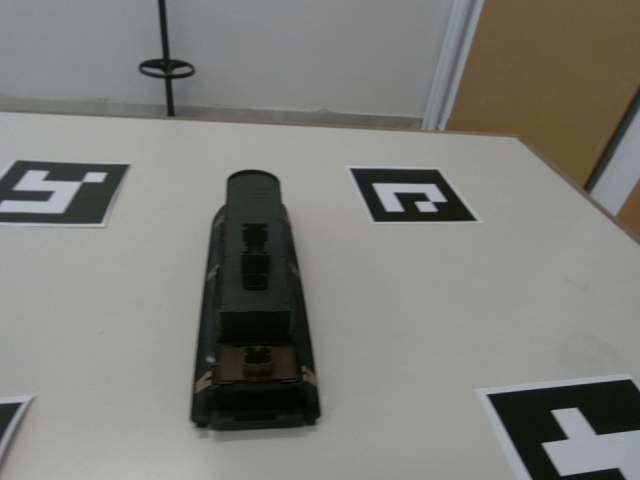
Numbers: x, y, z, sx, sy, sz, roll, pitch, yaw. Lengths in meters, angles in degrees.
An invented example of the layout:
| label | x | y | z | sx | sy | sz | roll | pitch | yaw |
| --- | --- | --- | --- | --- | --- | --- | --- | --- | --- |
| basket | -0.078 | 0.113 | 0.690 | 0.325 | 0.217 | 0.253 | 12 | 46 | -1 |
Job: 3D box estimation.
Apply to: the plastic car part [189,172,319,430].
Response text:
| label | x | y | z | sx | sy | sz | roll | pitch | yaw |
| --- | --- | --- | --- | --- | --- | --- | --- | --- | --- |
| plastic car part | -0.047 | 0.015 | 0.281 | 0.066 | 0.067 | 0.203 | -5 | 35 | -6 |
